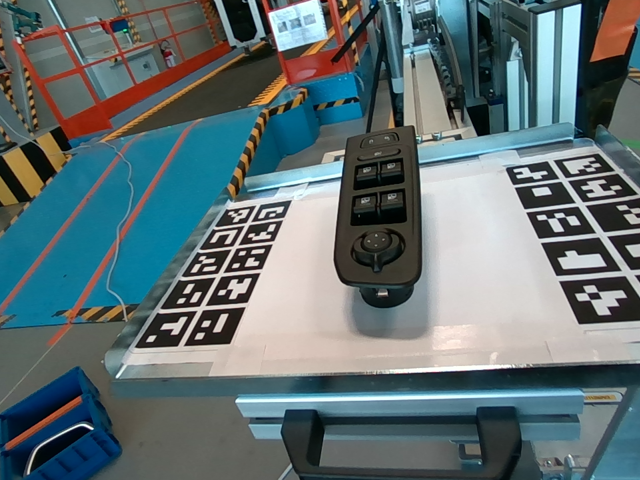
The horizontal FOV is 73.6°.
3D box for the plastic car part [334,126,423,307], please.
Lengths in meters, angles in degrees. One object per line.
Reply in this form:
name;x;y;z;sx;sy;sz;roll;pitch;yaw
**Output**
plastic car part;0.050;-0.022;0.355;0.066;0.067;0.202;-2;37;10
